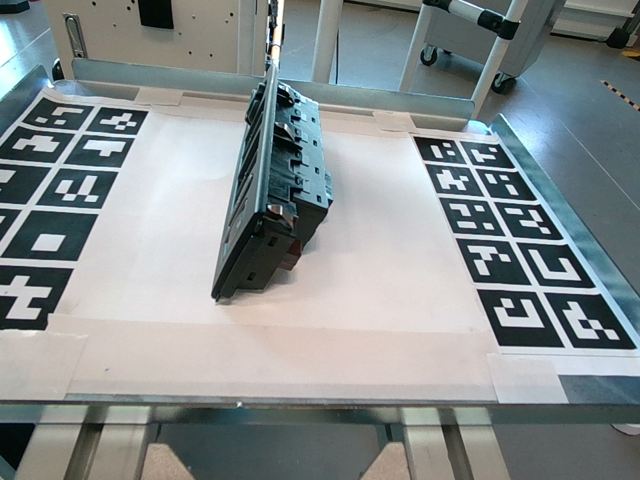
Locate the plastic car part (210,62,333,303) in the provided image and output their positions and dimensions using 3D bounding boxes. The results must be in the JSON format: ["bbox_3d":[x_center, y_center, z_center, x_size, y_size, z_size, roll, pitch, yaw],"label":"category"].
[{"bbox_3d":[-0.025,-0.053,0.279,0.067,0.202,0.066,11,-47,-19],"label":"plastic car part"}]
